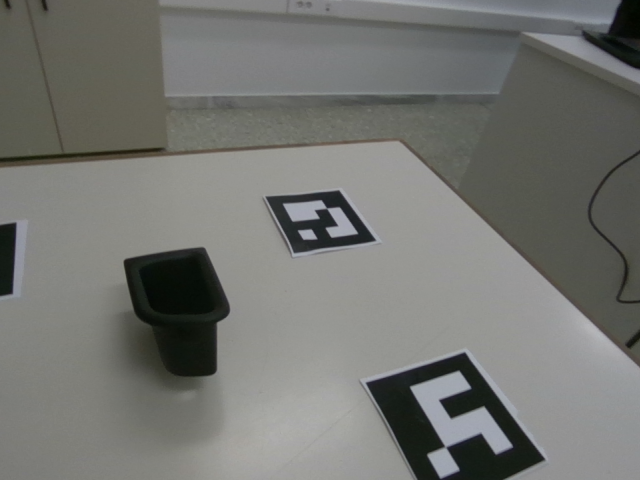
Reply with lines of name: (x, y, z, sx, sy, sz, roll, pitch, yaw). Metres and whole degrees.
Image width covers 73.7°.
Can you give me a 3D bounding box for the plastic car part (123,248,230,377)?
plastic car part: (-0.106, 0.060, 0.322, 0.065, 0.071, 0.117, -10, 28, -24)
